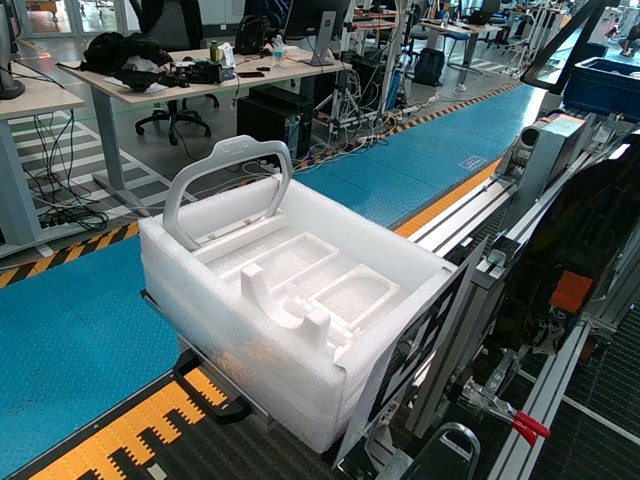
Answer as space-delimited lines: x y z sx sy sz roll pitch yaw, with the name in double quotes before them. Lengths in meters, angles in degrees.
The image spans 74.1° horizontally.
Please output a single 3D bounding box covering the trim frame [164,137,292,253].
"trim frame" -0.136 -0.072 0.675 0.247 0.185 0.027 -27 52 -37
